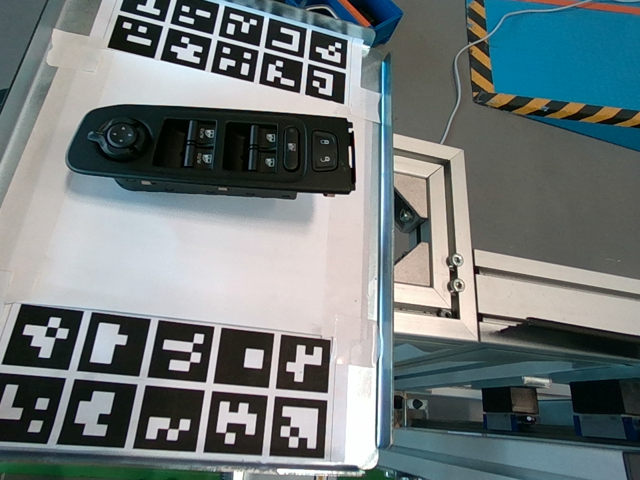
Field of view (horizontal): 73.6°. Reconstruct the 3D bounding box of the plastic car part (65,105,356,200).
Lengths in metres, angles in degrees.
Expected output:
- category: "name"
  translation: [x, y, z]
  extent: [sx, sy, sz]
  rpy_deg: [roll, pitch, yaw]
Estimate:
- category: "plastic car part"
  translation: [-0.078, -0.063, 0.328]
  extent: [0.203, 0.066, 0.067]
  rpy_deg: [4, -15, -10]
